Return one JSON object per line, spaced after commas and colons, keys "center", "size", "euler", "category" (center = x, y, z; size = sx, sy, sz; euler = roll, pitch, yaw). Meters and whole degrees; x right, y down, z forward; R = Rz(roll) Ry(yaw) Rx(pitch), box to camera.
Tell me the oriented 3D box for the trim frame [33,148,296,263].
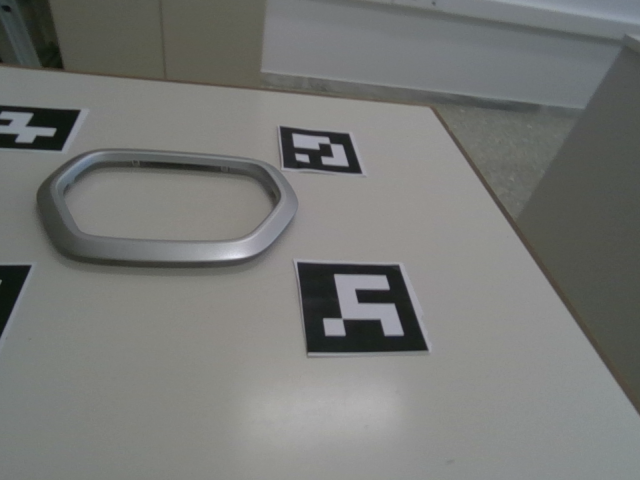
{"center": [-0.147, -0.043, 0.428], "size": [0.247, 0.027, 0.184], "euler": [0, 45, -12], "category": "trim frame"}
